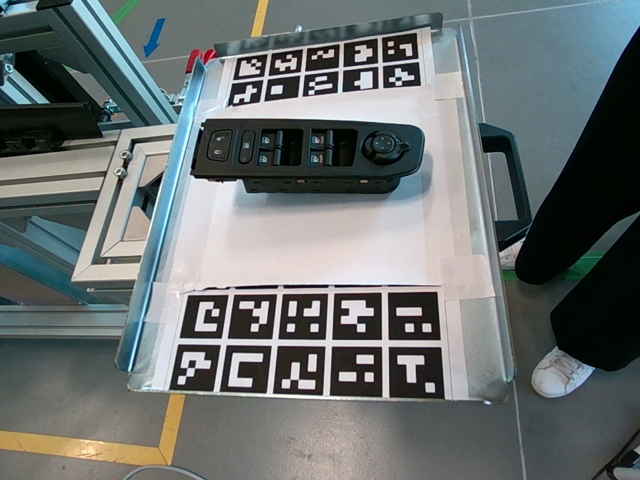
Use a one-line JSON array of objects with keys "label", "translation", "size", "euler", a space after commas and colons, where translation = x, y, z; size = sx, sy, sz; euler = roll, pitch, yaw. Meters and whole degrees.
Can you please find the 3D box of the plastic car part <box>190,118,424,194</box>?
[{"label": "plastic car part", "translation": [-0.008, -0.069, 0.391], "size": [0.203, 0.066, 0.067], "euler": [-1, -35, 7]}]
